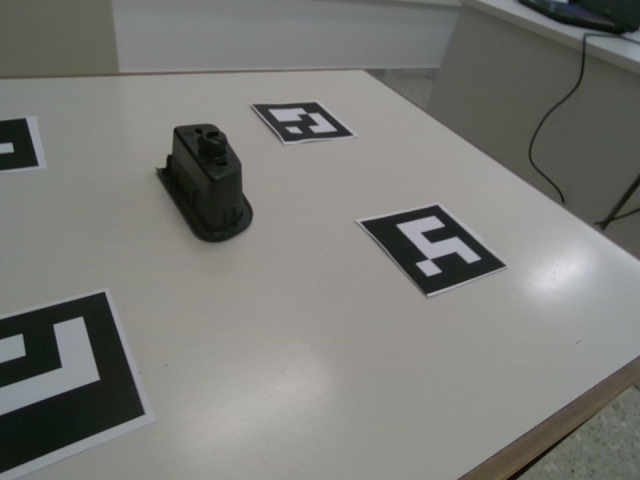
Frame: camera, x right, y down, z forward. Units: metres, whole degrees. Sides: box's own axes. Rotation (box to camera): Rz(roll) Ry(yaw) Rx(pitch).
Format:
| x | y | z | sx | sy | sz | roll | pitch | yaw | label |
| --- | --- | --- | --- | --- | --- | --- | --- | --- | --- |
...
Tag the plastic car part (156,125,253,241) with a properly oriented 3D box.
| x | y | z | sx | sy | sz | roll | pitch | yaw | label |
| --- | --- | --- | --- | --- | --- | --- | --- | --- | --- |
| -0.095 | -0.062 | 0.371 | 0.065 | 0.071 | 0.117 | -14 | 43 | -29 | plastic car part |
